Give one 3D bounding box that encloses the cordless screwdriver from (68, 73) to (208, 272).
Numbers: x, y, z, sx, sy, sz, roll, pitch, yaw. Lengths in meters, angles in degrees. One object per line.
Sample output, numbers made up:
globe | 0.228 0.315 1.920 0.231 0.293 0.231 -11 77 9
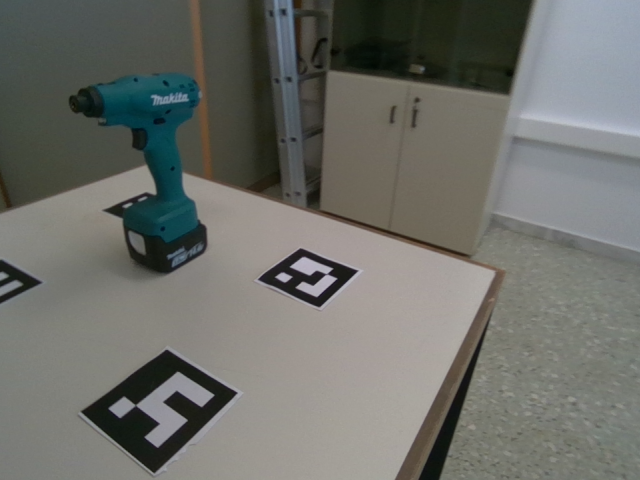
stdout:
cordless screwdriver | -0.221 -0.078 0.543 0.075 0.249 0.158 19 29 27
